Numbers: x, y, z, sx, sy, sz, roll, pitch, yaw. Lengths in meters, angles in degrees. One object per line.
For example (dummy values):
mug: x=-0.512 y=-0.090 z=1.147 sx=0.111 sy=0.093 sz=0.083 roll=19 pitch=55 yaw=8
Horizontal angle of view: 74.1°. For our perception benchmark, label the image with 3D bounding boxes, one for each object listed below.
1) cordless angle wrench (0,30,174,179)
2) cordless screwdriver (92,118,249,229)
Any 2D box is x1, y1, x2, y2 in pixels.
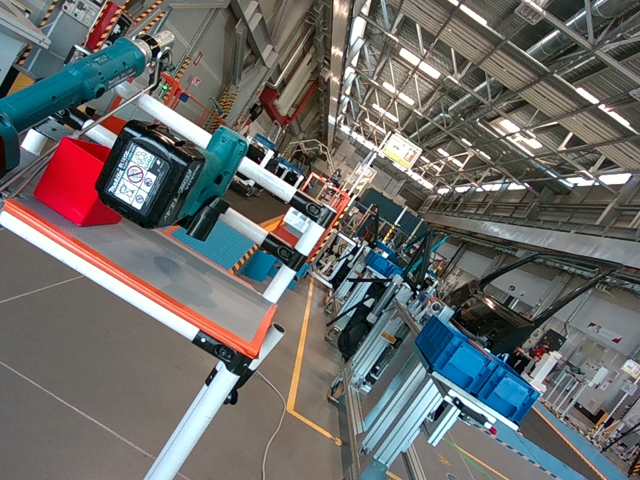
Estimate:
cordless angle wrench: x=-0.343 y=-0.227 z=0.610 sx=0.074 sy=0.421 sz=0.098 roll=35 pitch=-43 yaw=-6
cordless screwdriver: x=-0.170 y=-0.065 z=0.520 sx=0.074 sy=0.159 sz=0.248 roll=31 pitch=14 yaw=-1
